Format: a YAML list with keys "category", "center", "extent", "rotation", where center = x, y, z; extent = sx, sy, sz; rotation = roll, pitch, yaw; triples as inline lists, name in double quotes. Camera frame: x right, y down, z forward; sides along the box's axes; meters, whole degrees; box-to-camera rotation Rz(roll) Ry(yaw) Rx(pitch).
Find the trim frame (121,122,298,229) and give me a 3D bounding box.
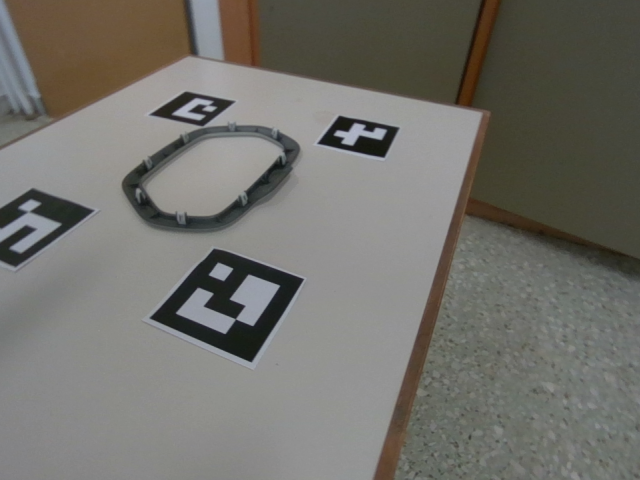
- category: "trim frame"
  center: [-0.129, -0.092, 0.536]
  extent: [0.185, 0.027, 0.247]
  rotation: [18, 42, 16]
